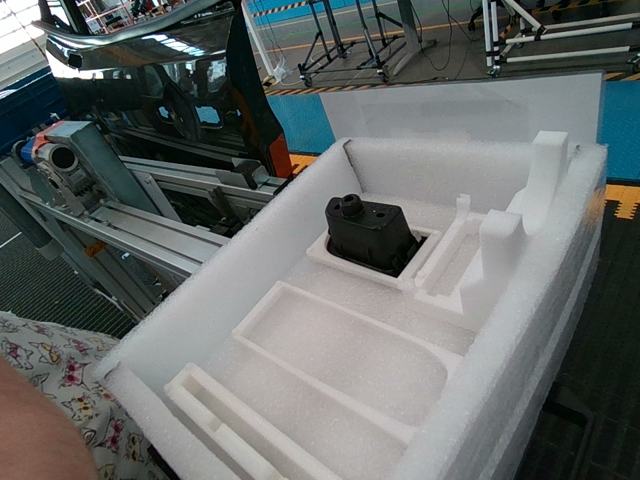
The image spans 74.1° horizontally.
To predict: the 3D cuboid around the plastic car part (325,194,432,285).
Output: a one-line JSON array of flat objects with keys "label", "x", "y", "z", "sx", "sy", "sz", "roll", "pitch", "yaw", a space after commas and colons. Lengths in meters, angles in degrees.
[{"label": "plastic car part", "x": 0.045, "y": -0.013, "z": 0.440, "sx": 0.117, "sy": 0.071, "sz": 0.065, "roll": 20, "pitch": 53, "yaw": 40}]
